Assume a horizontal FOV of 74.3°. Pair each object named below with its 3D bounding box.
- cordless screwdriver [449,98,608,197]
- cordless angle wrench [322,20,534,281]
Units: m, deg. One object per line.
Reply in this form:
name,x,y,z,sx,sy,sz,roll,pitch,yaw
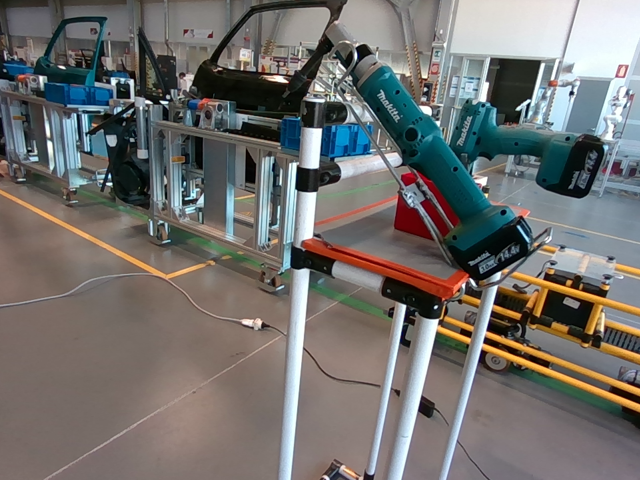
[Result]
cordless screwdriver,0.345,-0.138,0.741,0.249,0.159,0.074,28,28,28
cordless angle wrench,0.134,-0.143,0.593,0.098,0.422,0.074,-38,-9,30
